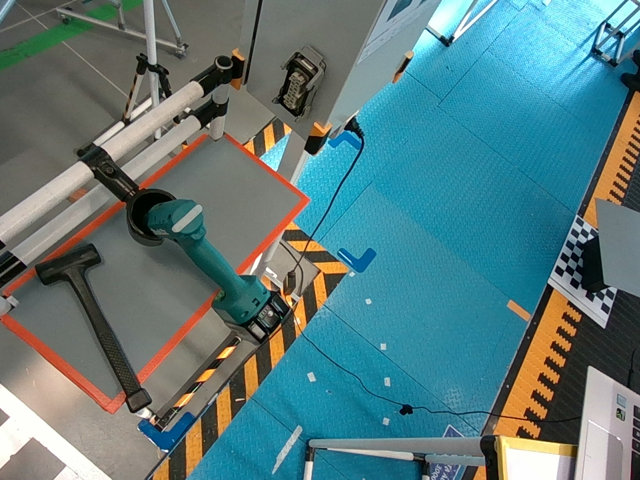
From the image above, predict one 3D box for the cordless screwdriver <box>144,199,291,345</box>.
[{"bbox_3d":[-0.164,0.045,0.639,0.159,0.249,0.074,1,42,52],"label":"cordless screwdriver"}]
